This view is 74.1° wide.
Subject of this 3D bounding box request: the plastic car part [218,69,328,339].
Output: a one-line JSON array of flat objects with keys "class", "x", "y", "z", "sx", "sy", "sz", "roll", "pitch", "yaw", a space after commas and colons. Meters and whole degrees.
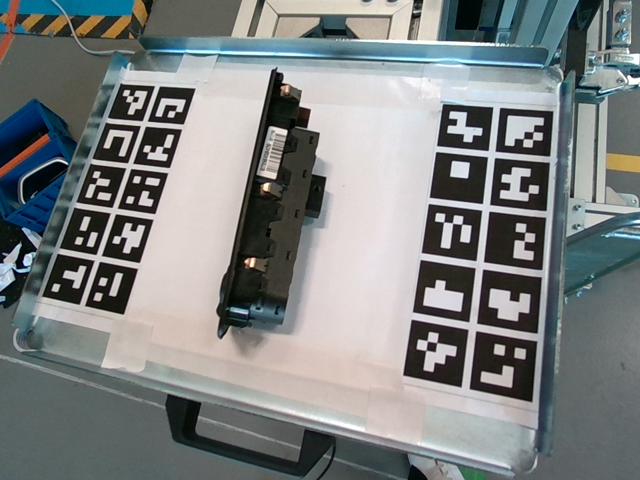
[{"class": "plastic car part", "x": -0.034, "y": -0.022, "z": 0.328, "sx": 0.067, "sy": 0.203, "sz": 0.067, "roll": 17, "pitch": -16, "yaw": -11}]
